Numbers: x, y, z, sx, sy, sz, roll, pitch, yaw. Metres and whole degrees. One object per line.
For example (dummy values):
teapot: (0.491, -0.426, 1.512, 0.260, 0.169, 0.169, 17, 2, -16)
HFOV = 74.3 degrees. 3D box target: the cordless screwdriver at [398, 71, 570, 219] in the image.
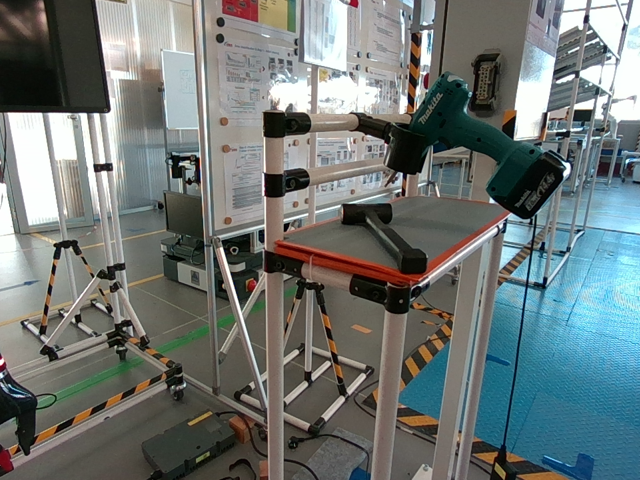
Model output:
cordless screwdriver: (0.243, -0.128, 0.666, 0.248, 0.160, 0.074, 45, 37, 16)
